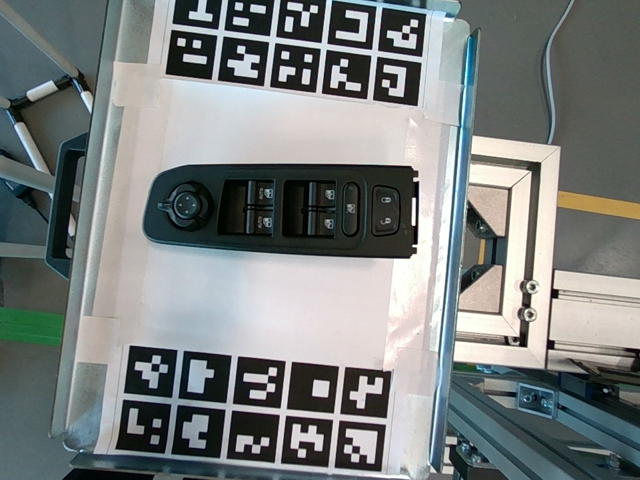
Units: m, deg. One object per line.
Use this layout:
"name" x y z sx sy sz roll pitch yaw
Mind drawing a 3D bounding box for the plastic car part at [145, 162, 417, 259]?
"plastic car part" -0.032 -0.026 0.329 0.203 0.066 0.067 2 7 4
